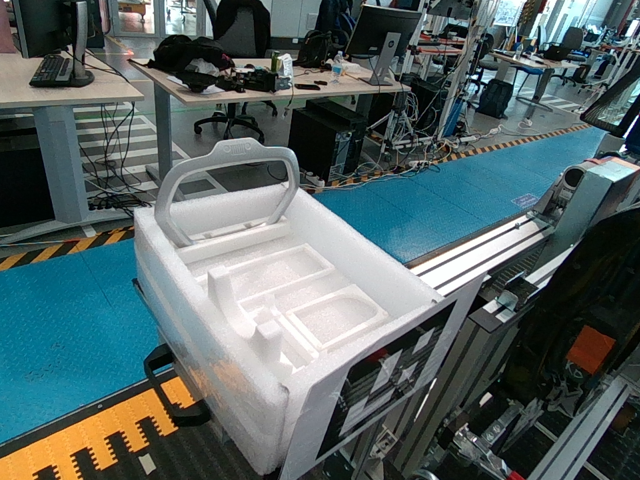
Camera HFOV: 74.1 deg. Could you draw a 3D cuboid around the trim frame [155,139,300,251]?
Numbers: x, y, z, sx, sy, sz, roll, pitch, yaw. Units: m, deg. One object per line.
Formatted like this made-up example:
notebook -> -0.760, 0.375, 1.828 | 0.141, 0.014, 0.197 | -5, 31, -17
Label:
trim frame -> -0.134, -0.068, 0.661 | 0.247, 0.185, 0.027 | -17, 49, -33
